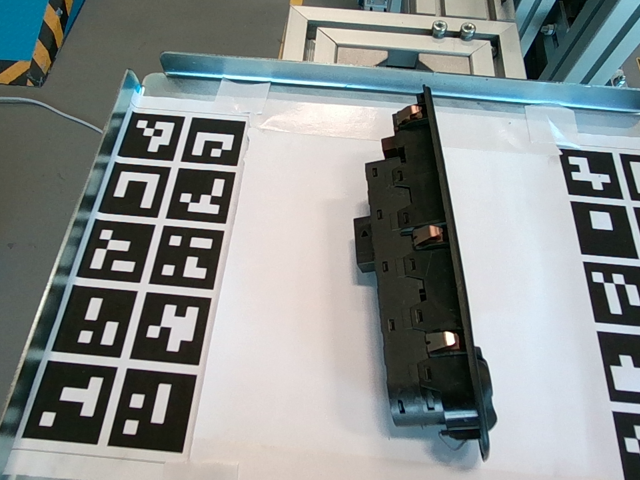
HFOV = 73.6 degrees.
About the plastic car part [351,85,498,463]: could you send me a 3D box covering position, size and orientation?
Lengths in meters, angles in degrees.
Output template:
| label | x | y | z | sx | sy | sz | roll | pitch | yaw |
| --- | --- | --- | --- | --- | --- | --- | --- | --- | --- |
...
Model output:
| label | x | y | z | sx | sy | sz | roll | pitch | yaw |
| --- | --- | --- | --- | --- | --- | --- | --- | --- | --- |
| plastic car part | 0.054 | 0.014 | 0.239 | 0.067 | 0.202 | 0.066 | -9 | -25 | 3 |
